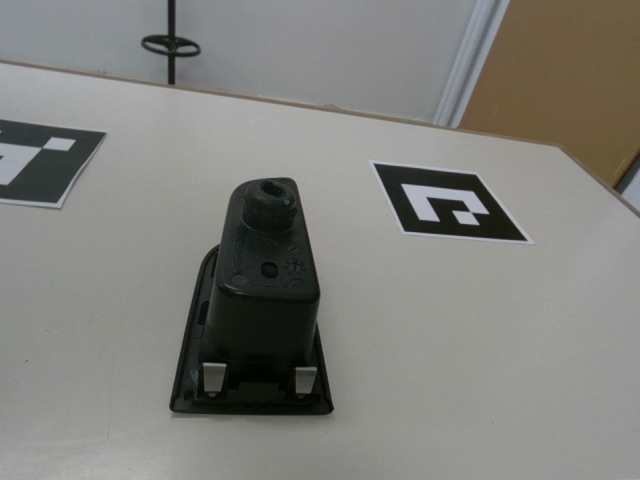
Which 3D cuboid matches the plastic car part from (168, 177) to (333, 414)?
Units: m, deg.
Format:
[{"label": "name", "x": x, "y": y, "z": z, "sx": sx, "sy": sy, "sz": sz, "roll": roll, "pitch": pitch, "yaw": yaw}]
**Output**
[{"label": "plastic car part", "x": -0.027, "y": 0.011, "z": 0.199, "sx": 0.066, "sy": 0.071, "sz": 0.117, "roll": 5, "pitch": 41, "yaw": -12}]
